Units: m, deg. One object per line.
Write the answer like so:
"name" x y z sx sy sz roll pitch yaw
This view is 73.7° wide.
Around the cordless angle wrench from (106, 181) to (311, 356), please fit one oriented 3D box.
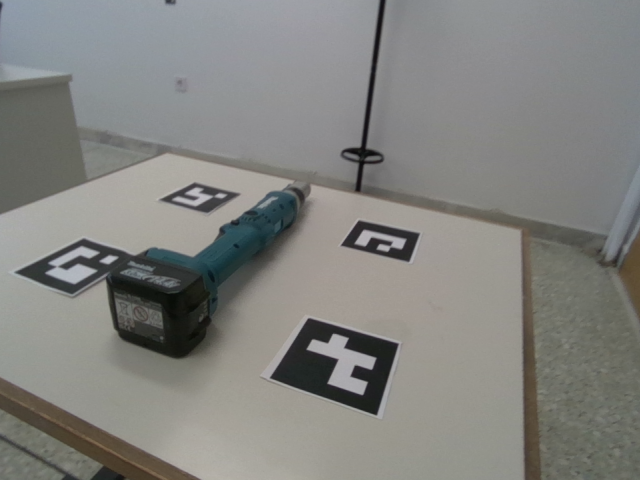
"cordless angle wrench" -0.096 -0.010 0.578 0.098 0.074 0.420 12 27 16
